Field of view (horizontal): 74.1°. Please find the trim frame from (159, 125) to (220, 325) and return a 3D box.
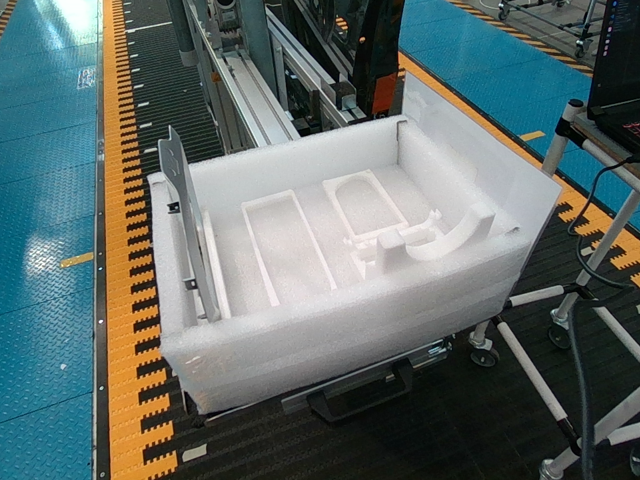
[{"bbox_3d":[-0.144,-0.018,0.469,0.027,0.248,0.184,-11,-42,-12],"label":"trim frame"}]
